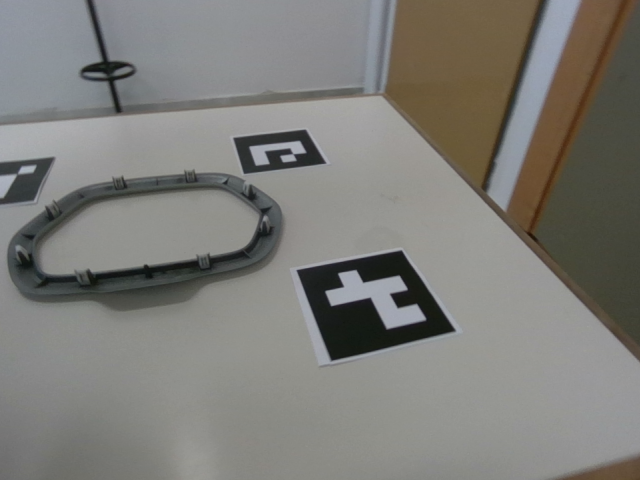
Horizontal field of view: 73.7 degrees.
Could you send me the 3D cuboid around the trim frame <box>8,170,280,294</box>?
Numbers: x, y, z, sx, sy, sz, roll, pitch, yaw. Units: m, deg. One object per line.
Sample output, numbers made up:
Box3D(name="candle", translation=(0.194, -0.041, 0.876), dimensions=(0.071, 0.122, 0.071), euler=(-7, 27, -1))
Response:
Box3D(name="trim frame", translation=(-0.162, -0.015, 0.410), dimensions=(0.247, 0.027, 0.185), euler=(-6, 41, -11))
